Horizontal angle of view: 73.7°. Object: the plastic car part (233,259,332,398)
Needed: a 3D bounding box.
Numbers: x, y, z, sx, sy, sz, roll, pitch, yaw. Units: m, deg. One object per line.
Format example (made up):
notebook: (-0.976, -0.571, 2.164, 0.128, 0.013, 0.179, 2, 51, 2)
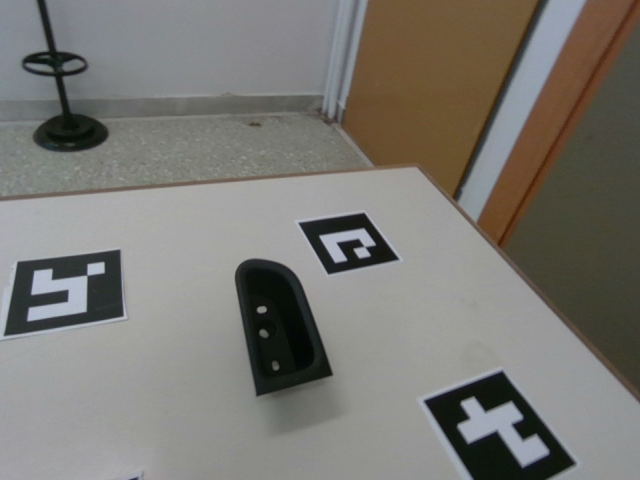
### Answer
plastic car part: (-0.044, 0.082, 0.388, 0.065, 0.117, 0.071, -8, -30, -20)
